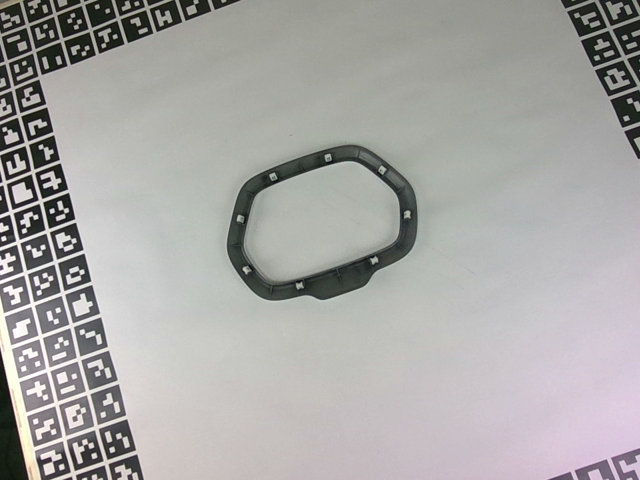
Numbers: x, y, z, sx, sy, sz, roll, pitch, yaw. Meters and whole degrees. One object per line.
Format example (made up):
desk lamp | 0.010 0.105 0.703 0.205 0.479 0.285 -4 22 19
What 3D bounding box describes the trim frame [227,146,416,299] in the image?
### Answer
trim frame | 0.001 -0.020 0.540 0.248 0.184 0.027 -17 -4 -1
